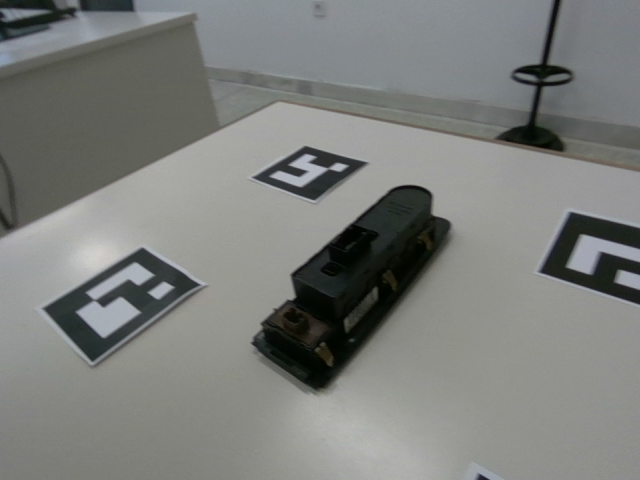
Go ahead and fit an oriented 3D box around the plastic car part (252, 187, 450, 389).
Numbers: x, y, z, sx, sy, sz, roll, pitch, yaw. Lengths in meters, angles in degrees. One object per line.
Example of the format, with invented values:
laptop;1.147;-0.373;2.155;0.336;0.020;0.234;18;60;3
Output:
plastic car part;0.034;0.015;0.334;0.067;0.067;0.201;15;39;39
